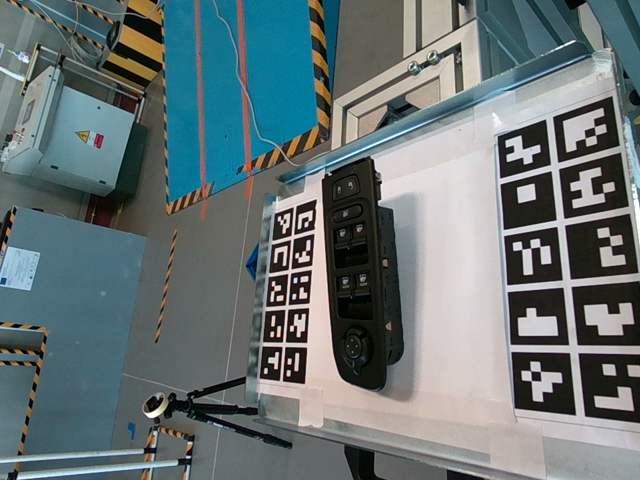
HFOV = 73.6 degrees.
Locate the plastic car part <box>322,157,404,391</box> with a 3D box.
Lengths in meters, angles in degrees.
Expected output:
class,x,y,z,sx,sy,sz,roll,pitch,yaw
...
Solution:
class,x,y,z,sx,sy,sz,roll,pitch,yaw
plastic car part,0.042,0.032,0.399,0.067,0.202,0.067,-11,-18,39
